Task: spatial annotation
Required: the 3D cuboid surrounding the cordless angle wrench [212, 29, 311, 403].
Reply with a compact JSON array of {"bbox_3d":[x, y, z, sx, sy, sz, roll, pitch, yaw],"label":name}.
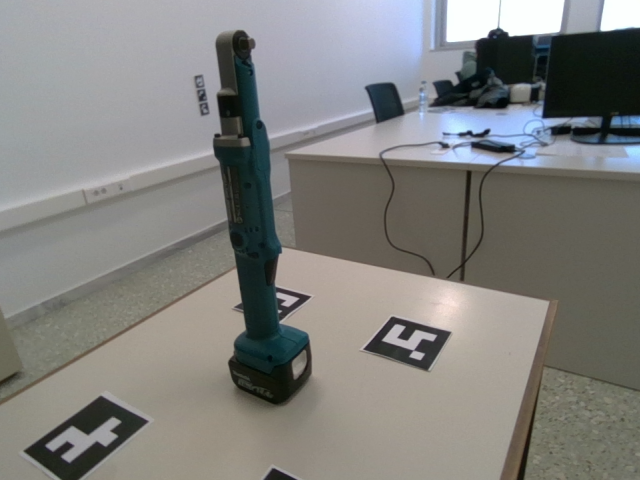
[{"bbox_3d":[-0.077,-0.009,0.495,0.099,0.422,0.074,10,25,31],"label":"cordless angle wrench"}]
